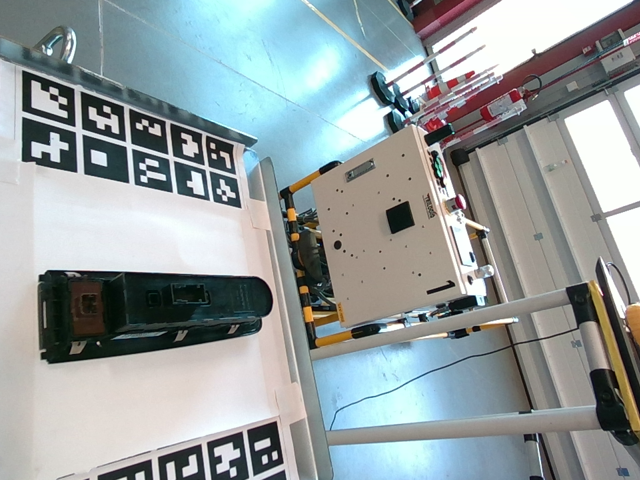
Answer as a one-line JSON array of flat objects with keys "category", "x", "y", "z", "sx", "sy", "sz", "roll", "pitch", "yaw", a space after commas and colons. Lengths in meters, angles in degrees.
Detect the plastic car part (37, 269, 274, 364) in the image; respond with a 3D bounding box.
[{"category": "plastic car part", "x": -0.113, "y": 0.052, "z": 0.359, "sx": 0.067, "sy": 0.066, "sz": 0.202, "roll": -32, "pitch": -24, "yaw": 29}]
